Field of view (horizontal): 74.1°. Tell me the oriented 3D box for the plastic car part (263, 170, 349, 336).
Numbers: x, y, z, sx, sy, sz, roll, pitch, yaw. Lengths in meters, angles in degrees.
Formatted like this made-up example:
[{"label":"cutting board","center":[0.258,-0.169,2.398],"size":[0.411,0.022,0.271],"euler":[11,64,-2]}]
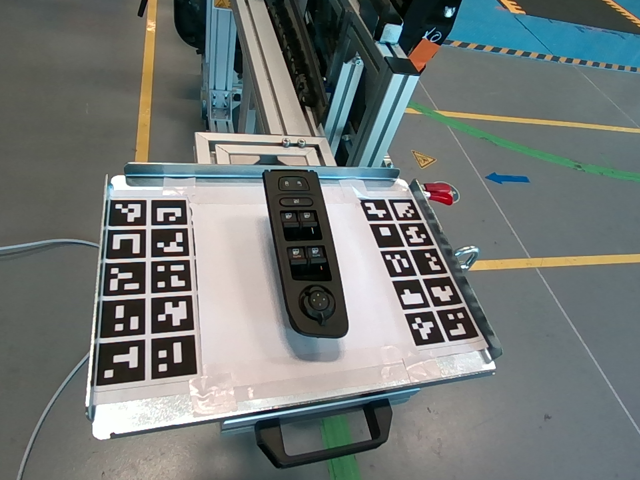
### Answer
[{"label":"plastic car part","center":[-0.022,0.016,0.465],"size":[0.066,0.203,0.067],"euler":[2,-35,-25]}]
